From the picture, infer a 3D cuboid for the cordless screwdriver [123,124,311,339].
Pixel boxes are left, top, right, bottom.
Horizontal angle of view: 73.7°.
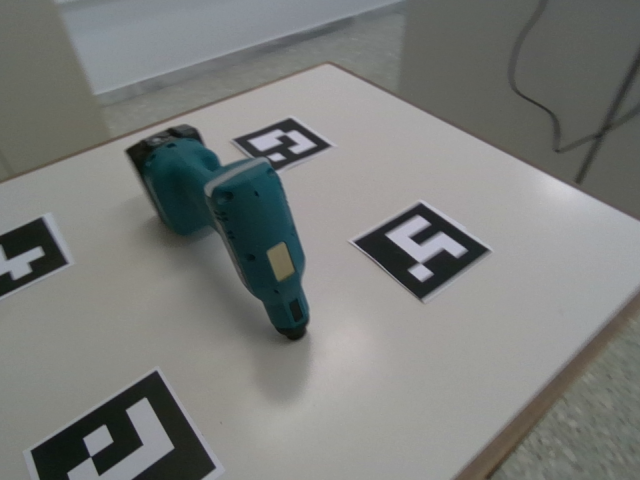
[{"bbox_3d":[-0.095,-0.018,0.401,0.074,0.158,0.251,-32,36,-22],"label":"cordless screwdriver"}]
